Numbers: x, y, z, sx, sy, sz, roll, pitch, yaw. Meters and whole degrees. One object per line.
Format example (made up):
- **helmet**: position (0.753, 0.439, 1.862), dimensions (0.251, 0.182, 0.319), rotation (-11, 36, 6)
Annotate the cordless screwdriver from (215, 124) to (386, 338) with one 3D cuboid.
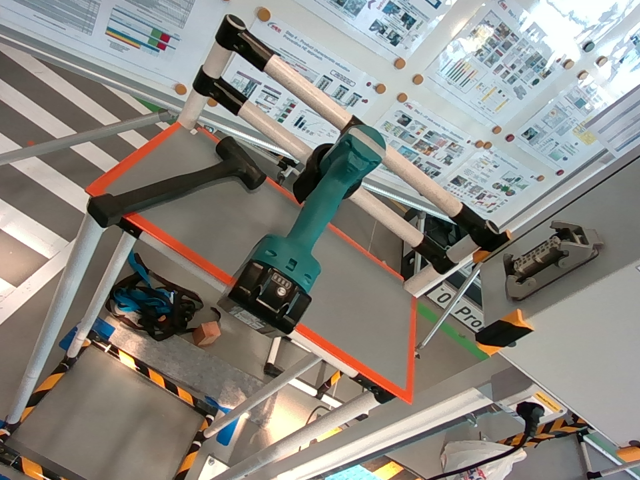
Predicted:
- **cordless screwdriver**: position (-0.023, -0.012, 0.494), dimensions (0.074, 0.248, 0.159), rotation (35, -21, -11)
